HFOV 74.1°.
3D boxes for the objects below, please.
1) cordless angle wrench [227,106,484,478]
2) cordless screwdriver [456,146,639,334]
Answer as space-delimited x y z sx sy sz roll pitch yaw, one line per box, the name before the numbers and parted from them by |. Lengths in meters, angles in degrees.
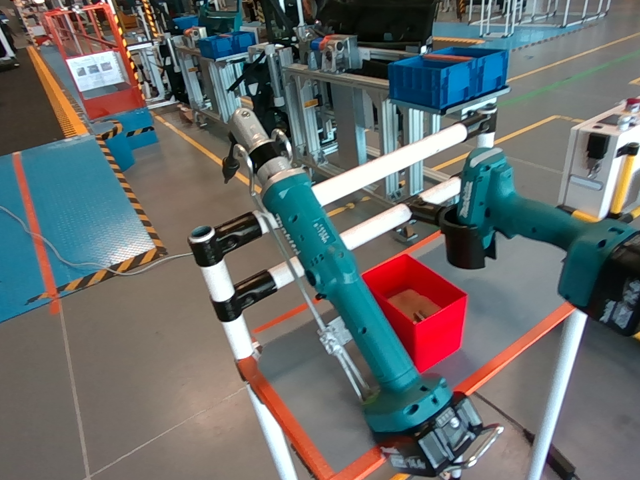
cordless angle wrench | 0.010 0.031 0.451 0.074 0.422 0.098 -26 -11 -30
cordless screwdriver | 0.260 0.008 0.495 0.074 0.159 0.248 -25 45 -23
